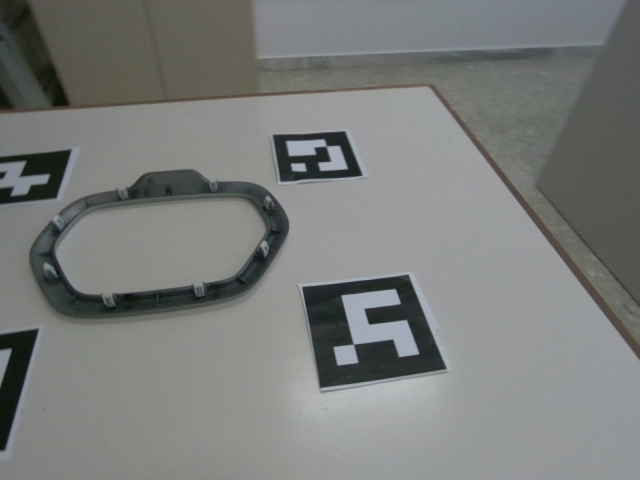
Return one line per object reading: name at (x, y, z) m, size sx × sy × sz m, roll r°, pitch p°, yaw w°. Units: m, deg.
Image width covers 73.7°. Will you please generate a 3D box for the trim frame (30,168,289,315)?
trim frame at (-0.154, -0.008, 0.422) m, size 0.248 × 0.184 × 0.027 m, roll -7°, pitch -44°, yaw -4°
